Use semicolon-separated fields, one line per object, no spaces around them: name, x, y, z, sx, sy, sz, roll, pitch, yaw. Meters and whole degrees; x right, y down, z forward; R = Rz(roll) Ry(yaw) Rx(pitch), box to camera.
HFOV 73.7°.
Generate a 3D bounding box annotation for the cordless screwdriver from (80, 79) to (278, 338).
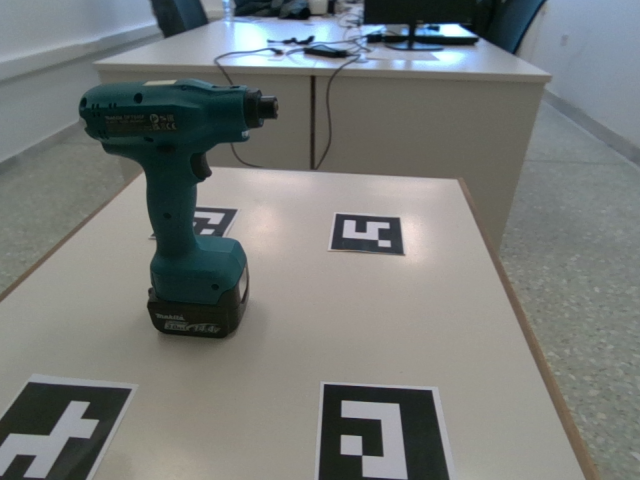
cordless screwdriver;-0.109;-0.022;0.406;0.159;0.248;0.074;1;31;8
